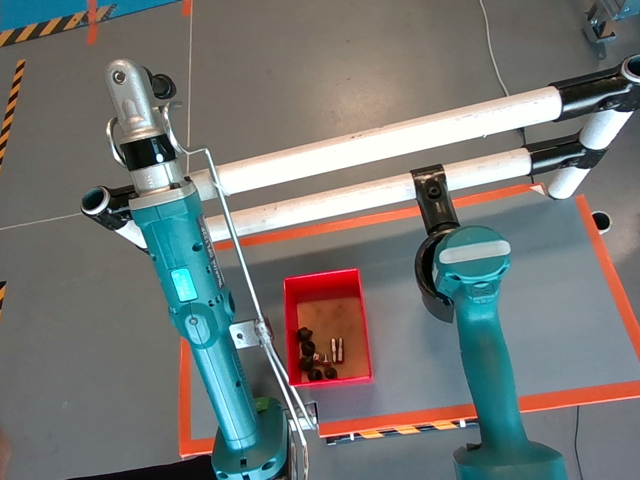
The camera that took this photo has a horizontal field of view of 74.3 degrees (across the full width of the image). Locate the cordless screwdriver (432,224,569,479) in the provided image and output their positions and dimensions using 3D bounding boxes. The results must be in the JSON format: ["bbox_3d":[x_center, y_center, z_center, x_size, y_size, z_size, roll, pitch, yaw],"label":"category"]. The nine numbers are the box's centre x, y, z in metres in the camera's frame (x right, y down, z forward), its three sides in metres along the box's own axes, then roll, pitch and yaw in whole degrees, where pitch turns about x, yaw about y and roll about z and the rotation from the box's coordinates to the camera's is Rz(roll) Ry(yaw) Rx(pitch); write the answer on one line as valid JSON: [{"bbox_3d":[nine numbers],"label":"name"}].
[{"bbox_3d":[0.136,0.123,0.343,0.074,0.248,0.159,-9,-17,10],"label":"cordless screwdriver"}]

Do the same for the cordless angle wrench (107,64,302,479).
[{"bbox_3d":[-0.104,0.061,0.385,0.074,0.423,0.098,-13,15,4],"label":"cordless angle wrench"}]
